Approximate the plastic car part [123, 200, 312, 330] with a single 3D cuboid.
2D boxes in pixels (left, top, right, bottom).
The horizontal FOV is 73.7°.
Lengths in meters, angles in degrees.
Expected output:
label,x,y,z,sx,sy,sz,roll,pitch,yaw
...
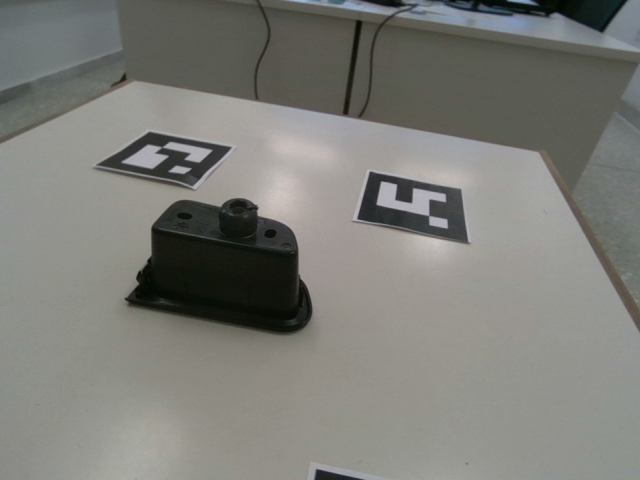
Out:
label,x,y,z,sx,sy,sz,roll,pitch,yaw
plastic car part,-0.059,0.007,0.272,0.117,0.071,0.066,8,36,7
